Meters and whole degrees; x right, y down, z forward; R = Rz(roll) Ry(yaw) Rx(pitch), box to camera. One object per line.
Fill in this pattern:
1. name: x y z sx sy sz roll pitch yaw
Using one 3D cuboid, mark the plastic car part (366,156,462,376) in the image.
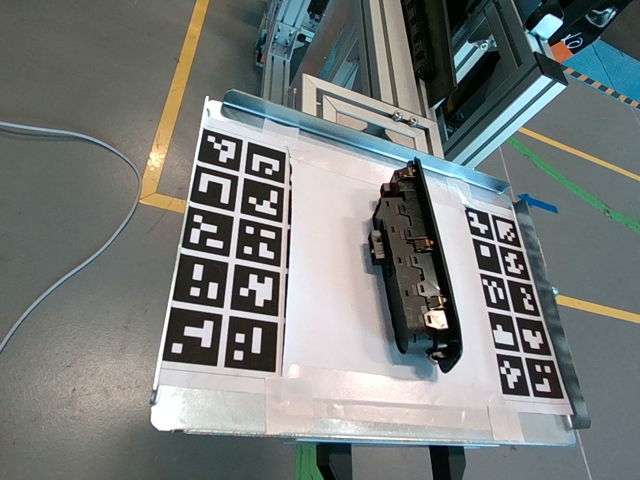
1. plastic car part: 0.083 0.022 0.394 0.067 0.202 0.066 -4 -26 -15
